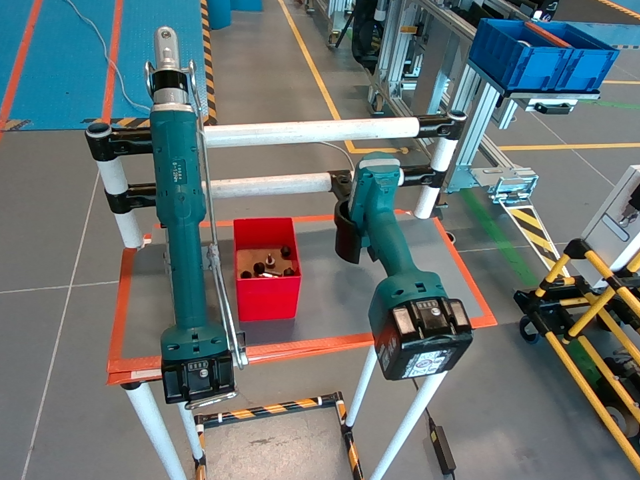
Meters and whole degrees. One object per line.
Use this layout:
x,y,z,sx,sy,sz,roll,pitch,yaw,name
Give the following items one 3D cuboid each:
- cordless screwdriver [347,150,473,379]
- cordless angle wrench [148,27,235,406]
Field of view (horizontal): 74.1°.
0.080,0.035,0.497,0.074,0.248,0.159,-5,-35,-11,cordless screwdriver
-0.160,-0.038,0.486,0.074,0.422,0.098,-5,-4,-19,cordless angle wrench
